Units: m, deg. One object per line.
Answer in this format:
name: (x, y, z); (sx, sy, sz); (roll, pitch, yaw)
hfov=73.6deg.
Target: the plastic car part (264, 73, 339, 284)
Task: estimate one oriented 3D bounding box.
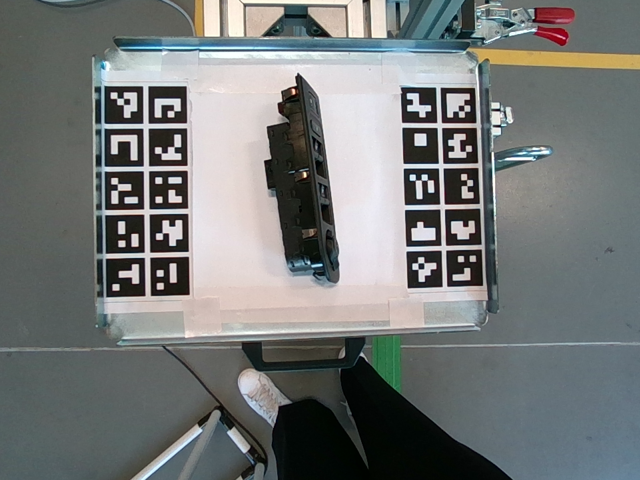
plastic car part: (-0.019, -0.053, 0.425); (0.067, 0.203, 0.066); (-12, -4, 9)
